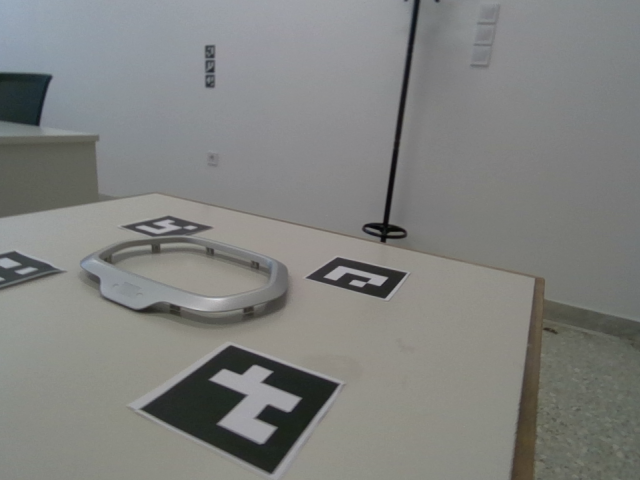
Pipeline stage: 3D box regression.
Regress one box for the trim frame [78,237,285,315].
[{"bbox_3d":[-0.155,0.036,0.492,0.250,0.027,0.182,15,18,25],"label":"trim frame"}]
